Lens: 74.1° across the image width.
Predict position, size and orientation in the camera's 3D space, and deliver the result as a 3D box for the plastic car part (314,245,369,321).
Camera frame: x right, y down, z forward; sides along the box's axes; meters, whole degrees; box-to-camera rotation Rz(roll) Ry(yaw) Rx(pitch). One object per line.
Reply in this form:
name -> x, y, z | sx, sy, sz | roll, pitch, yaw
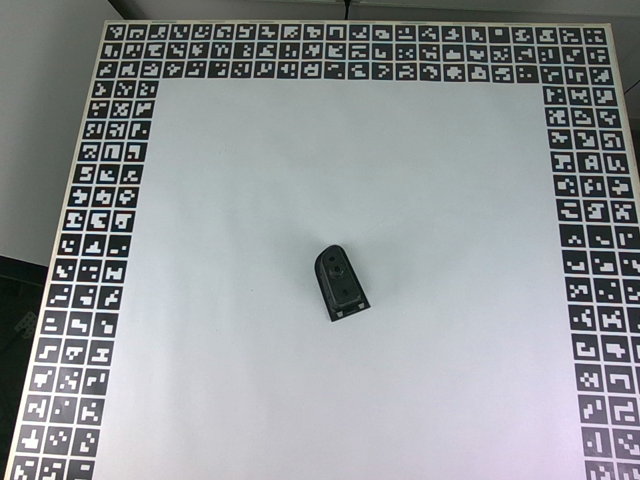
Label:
plastic car part -> 0.028, 0.059, 0.664 | 0.066, 0.116, 0.071 | -21, -12, -5
